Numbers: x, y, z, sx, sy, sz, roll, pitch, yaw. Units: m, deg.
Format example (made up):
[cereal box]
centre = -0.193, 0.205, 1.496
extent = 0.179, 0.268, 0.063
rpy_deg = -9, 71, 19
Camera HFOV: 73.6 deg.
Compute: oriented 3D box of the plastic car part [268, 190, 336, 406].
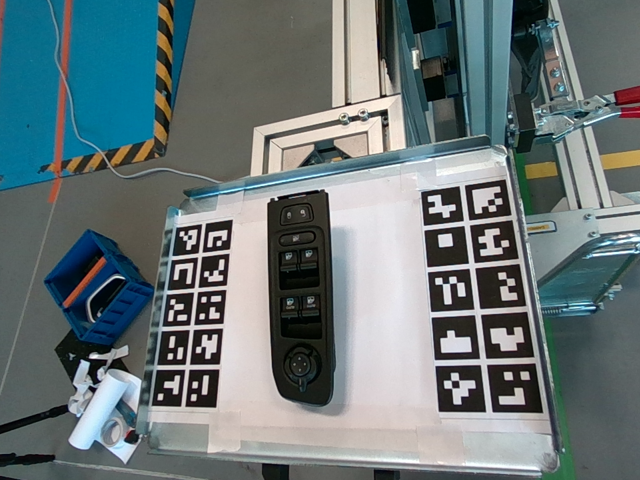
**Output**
[plastic car part]
centre = -0.014, 0.057, 0.427
extent = 0.066, 0.202, 0.067
rpy_deg = -5, -18, 11
